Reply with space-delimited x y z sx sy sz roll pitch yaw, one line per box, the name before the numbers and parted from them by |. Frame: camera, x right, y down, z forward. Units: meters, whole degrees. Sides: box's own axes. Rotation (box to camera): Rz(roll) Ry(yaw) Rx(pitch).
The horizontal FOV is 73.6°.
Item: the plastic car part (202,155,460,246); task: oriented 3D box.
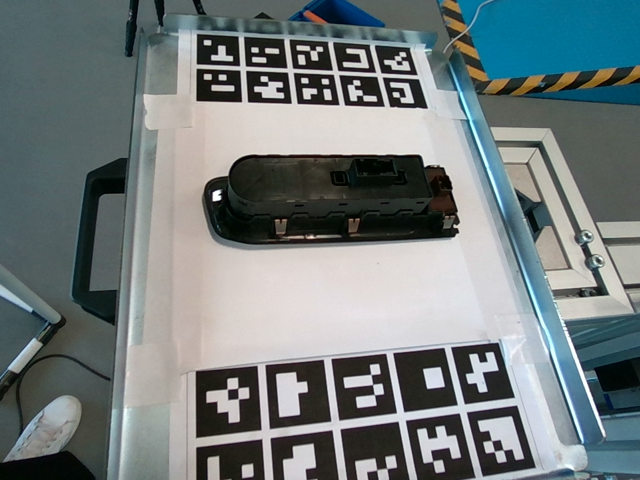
plastic car part | 0.015 -0.033 0.321 0.203 0.066 0.067 -4 -19 -10
